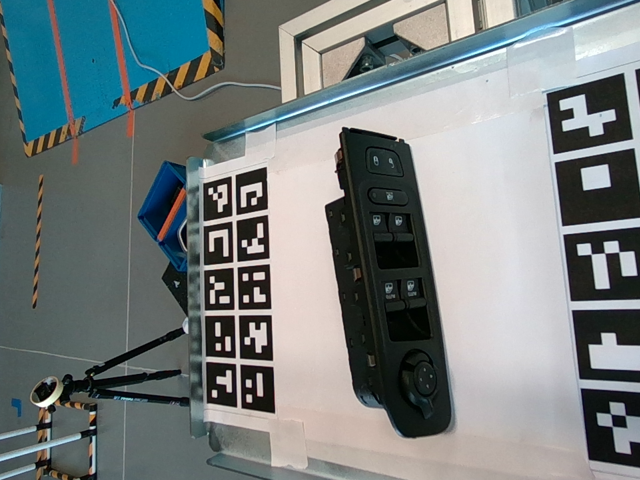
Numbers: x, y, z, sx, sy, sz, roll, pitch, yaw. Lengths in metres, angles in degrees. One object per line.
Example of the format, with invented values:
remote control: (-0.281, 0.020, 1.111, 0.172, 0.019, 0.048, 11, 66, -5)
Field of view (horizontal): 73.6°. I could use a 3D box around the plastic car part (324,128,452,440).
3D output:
plastic car part: (0.038, 0.030, 0.291, 0.066, 0.202, 0.067, 2, -18, -45)
